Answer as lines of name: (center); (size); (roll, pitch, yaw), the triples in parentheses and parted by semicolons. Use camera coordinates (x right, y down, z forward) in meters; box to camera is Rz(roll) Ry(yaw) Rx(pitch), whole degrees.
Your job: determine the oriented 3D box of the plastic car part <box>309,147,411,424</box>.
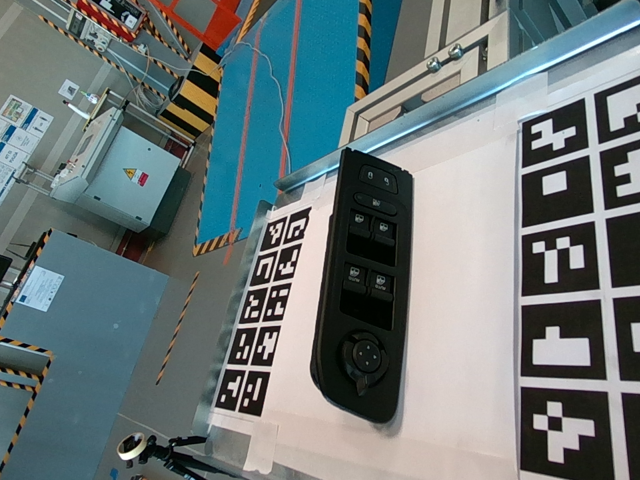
plastic car part: (0.024, 0.028, 0.315); (0.066, 0.202, 0.067); (22, -37, -23)
